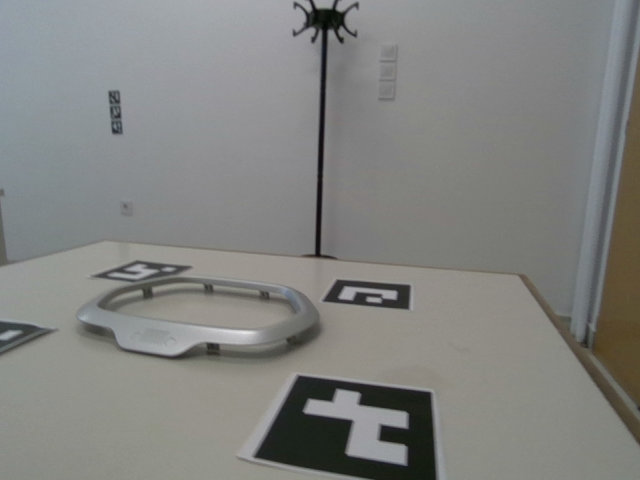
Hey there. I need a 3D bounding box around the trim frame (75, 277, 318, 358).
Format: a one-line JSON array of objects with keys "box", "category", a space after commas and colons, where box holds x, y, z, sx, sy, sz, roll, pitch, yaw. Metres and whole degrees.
[{"box": [-0.124, 0.073, 0.445, 0.250, 0.027, 0.183, 6, 10, 14], "category": "trim frame"}]
